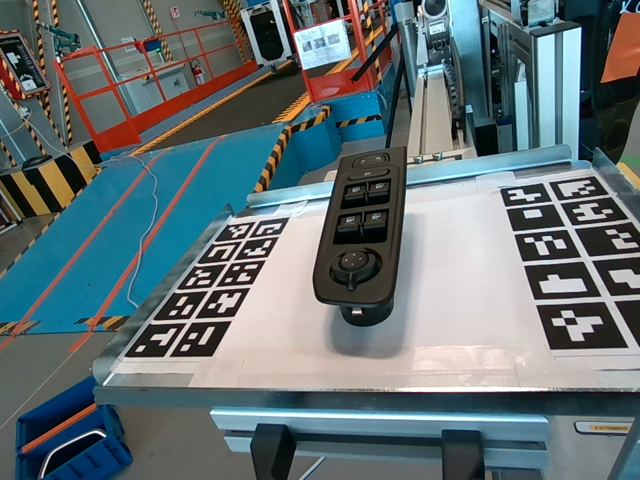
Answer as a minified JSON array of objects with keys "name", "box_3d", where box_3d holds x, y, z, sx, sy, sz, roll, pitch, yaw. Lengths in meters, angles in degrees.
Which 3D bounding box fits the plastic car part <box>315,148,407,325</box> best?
[{"name":"plastic car part","box_3d":[0.040,-0.006,0.360,0.066,0.067,0.202,-1,35,13]}]
